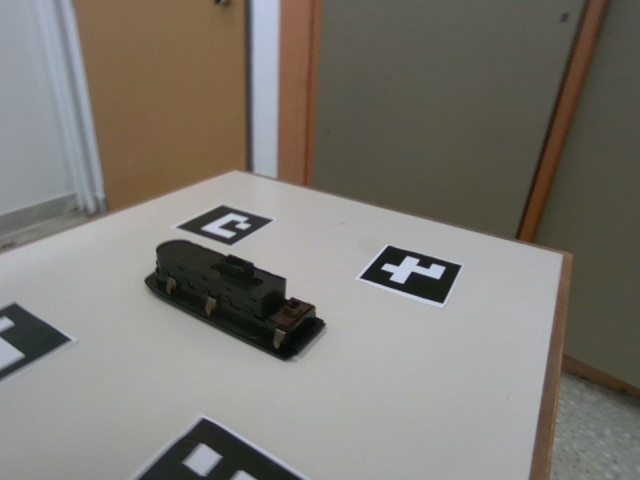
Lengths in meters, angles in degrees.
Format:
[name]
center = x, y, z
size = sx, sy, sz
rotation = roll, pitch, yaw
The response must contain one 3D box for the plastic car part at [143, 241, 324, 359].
[plastic car part]
center = -0.098, 0.047, 0.425
size = 0.205, 0.067, 0.066
rotation = 14, 34, 28
